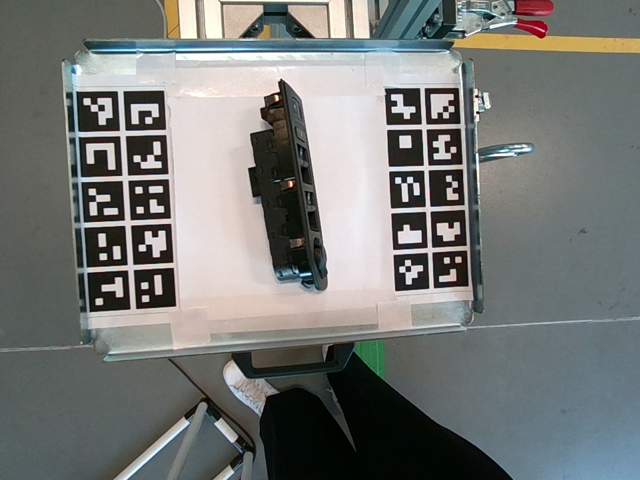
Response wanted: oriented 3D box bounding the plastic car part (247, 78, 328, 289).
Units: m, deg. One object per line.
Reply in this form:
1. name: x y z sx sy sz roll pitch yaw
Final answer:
1. plastic car part: -0.033 -0.045 0.415 0.067 0.203 0.066 -13 1 6
